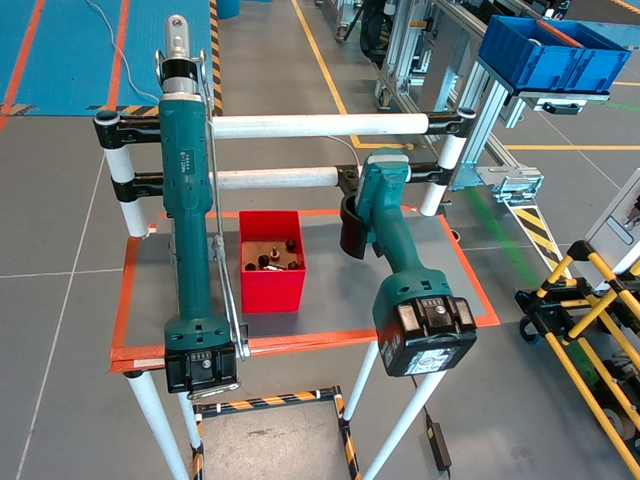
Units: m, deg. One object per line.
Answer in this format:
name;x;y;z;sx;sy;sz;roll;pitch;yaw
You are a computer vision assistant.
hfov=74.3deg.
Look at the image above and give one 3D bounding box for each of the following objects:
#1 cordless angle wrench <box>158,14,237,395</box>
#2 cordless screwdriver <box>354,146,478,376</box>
cordless angle wrench;-0.151;-0.048;0.484;0.074;0.422;0.098;-4;-2;-19
cordless screwdriver;0.086;0.031;0.496;0.074;0.248;0.160;-4;-33;-10
